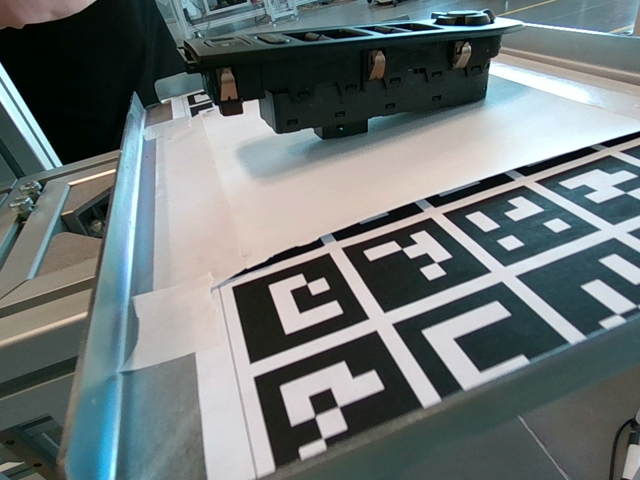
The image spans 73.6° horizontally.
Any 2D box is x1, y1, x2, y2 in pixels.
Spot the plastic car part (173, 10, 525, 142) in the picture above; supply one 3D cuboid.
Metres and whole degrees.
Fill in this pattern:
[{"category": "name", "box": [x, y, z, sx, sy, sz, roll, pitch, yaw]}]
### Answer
[{"category": "plastic car part", "box": [0.027, -0.097, 0.248, 0.202, 0.067, 0.066, -17, 27, -13]}]
